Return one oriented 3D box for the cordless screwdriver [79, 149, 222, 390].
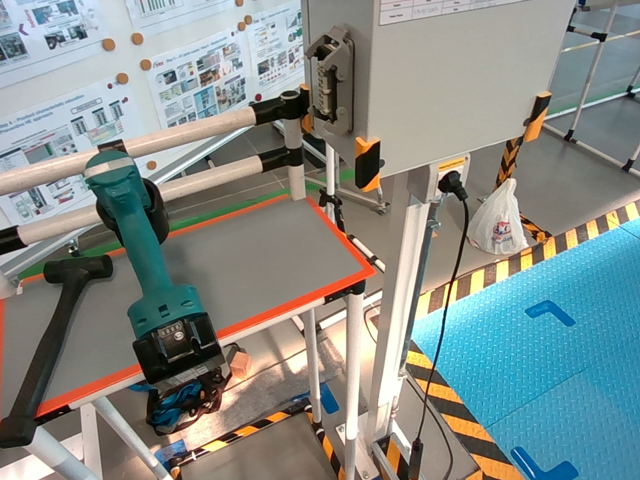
[{"bbox_3d":[-0.190,0.037,0.479,0.074,0.248,0.160,-22,-15,-17],"label":"cordless screwdriver"}]
